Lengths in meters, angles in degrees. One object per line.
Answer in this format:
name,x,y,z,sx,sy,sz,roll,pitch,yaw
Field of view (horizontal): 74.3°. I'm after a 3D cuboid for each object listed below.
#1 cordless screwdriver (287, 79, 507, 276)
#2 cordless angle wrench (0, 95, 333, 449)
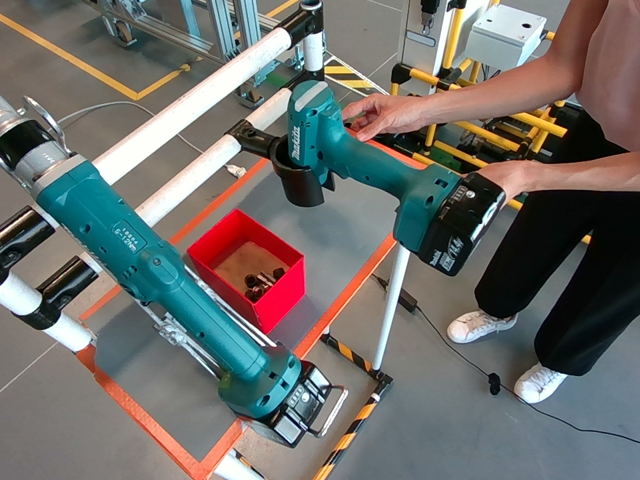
cordless screwdriver,0.065,-0.058,0.477,0.248,0.074,0.159,36,-24,15
cordless angle wrench,-0.153,0.027,0.385,0.098,0.423,0.074,-14,30,54
